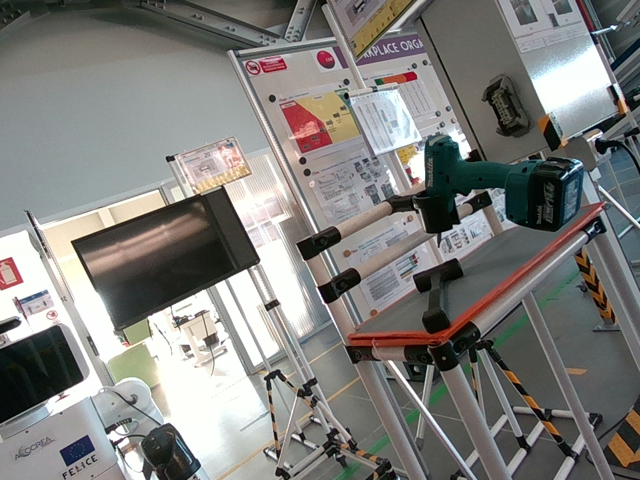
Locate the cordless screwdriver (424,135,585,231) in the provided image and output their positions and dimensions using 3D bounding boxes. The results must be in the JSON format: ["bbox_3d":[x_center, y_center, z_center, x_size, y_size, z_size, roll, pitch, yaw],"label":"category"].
[{"bbox_3d":[0.276,-0.074,0.684,0.074,0.159,0.249,-28,35,-32],"label":"cordless screwdriver"}]
